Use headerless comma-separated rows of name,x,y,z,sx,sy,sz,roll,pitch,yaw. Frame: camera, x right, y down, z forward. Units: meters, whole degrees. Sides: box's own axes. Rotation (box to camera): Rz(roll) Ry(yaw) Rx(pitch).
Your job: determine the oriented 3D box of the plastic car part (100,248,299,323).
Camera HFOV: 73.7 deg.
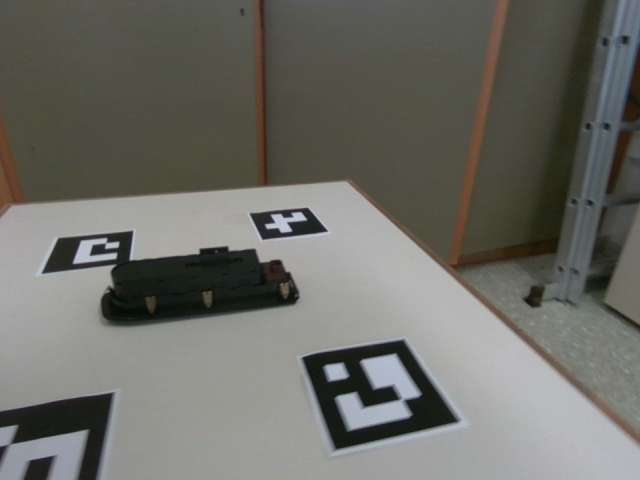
plastic car part,-0.127,0.045,0.450,0.202,0.067,0.066,-9,33,-13
